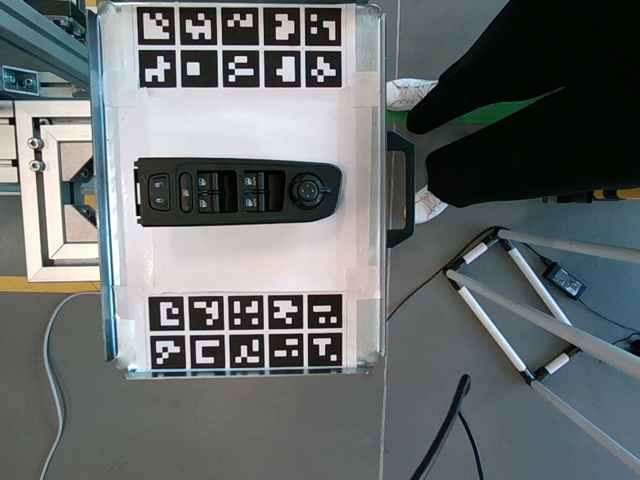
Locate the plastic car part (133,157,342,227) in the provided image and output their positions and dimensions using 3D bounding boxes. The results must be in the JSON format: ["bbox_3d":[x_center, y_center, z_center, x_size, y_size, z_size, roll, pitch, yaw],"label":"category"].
[{"bbox_3d":[-0.079,-0.047,0.442,0.203,0.066,0.067,-2,-3,-5],"label":"plastic car part"}]
